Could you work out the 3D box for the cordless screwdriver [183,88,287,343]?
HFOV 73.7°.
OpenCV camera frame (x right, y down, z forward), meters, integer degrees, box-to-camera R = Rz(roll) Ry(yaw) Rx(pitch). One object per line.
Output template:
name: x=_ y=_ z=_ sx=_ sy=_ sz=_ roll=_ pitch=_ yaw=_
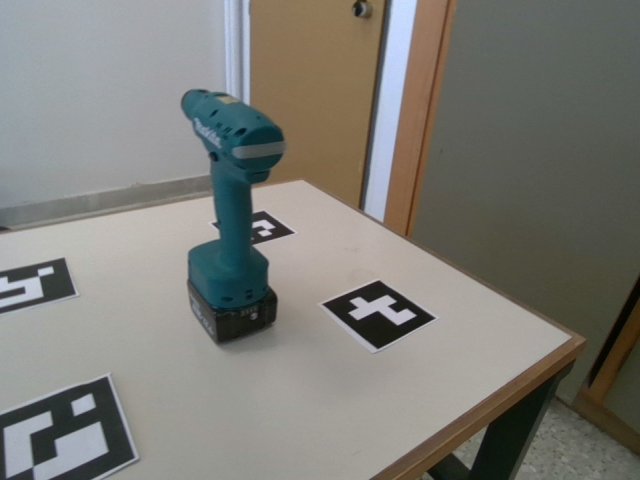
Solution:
cordless screwdriver: x=-0.103 y=-0.026 z=0.450 sx=0.073 sy=0.249 sz=0.160 roll=-14 pitch=37 yaw=-32
